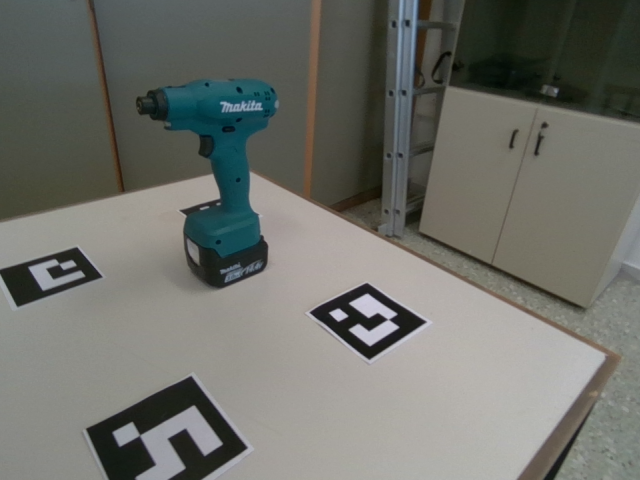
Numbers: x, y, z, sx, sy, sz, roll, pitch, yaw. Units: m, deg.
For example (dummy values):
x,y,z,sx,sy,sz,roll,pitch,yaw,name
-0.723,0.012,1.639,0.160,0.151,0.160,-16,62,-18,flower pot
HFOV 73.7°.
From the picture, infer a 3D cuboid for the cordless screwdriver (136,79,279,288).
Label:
x,y,z,sx,sy,sz,roll,pitch,yaw,name
-0.133,-0.063,0.517,0.157,0.249,0.075,-17,34,-39,cordless screwdriver
